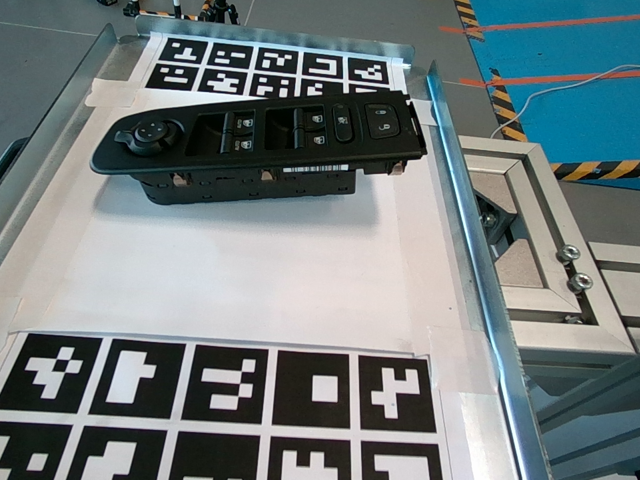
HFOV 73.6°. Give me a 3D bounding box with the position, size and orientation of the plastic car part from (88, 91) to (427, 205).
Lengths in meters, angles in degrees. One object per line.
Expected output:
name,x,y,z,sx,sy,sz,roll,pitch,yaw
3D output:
plastic car part,-0.041,-0.057,0.284,0.203,0.066,0.067,-1,-30,-4
